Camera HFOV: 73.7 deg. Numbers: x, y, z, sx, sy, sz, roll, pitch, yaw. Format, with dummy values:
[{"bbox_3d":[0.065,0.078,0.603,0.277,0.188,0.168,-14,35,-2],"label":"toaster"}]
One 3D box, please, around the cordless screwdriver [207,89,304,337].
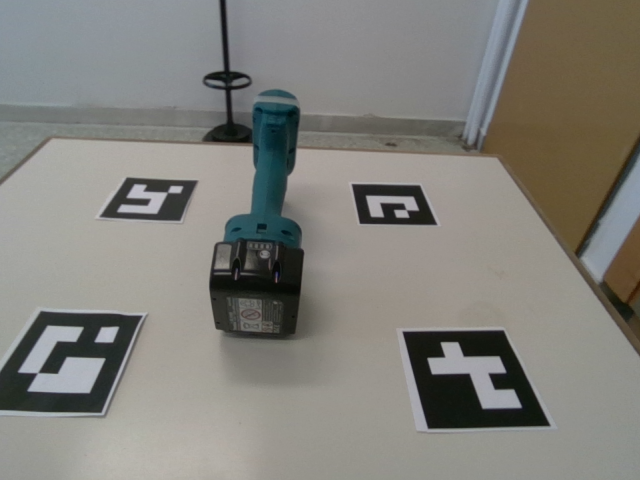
[{"bbox_3d":[-0.056,-0.020,0.445,0.074,0.249,0.159,5,-37,-5],"label":"cordless screwdriver"}]
